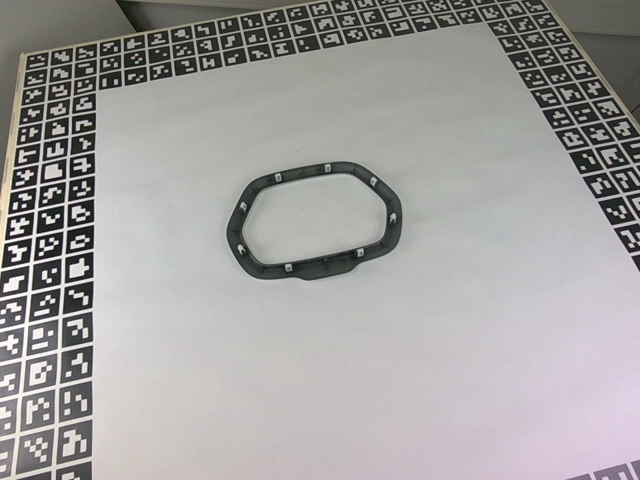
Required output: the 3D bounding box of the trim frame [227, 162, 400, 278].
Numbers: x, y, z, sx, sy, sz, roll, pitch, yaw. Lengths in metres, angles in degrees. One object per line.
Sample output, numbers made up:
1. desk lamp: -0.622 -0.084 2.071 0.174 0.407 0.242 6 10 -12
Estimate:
1. trim frame: -0.007 -0.031 0.601 0.248 0.184 0.027 -10 -25 -8
